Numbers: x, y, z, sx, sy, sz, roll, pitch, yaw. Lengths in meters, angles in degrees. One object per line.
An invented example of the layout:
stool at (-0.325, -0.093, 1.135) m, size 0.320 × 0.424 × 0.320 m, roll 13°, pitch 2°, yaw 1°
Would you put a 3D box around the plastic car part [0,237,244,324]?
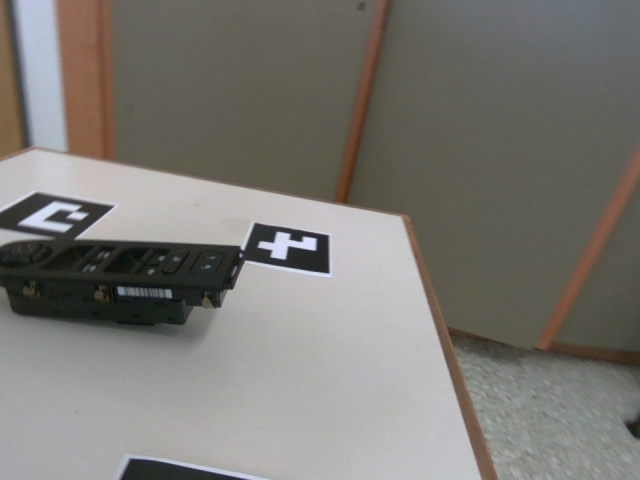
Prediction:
plastic car part at (-0.166, 0.032, 0.338) m, size 0.203 × 0.067 × 0.066 m, roll 6°, pitch 37°, yaw 0°
